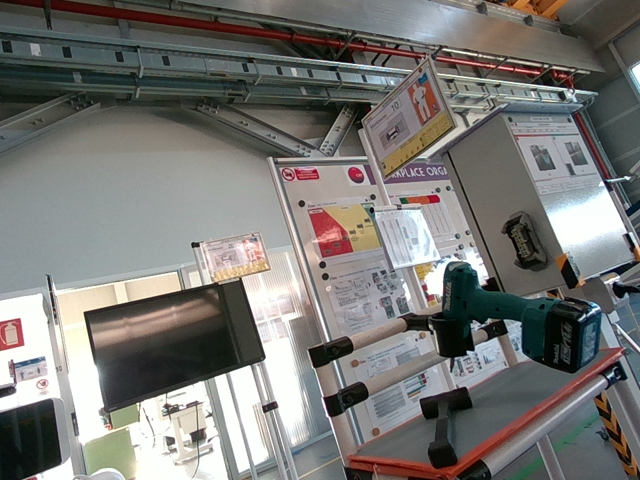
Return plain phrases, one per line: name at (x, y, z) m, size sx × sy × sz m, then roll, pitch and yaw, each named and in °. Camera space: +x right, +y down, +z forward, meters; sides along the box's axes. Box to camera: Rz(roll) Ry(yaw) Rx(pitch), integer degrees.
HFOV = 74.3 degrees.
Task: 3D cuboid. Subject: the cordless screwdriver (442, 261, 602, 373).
cordless screwdriver at (0.305, 0.139, 0.690) m, size 0.074 × 0.159 × 0.249 m, roll -12°, pitch 19°, yaw -34°
